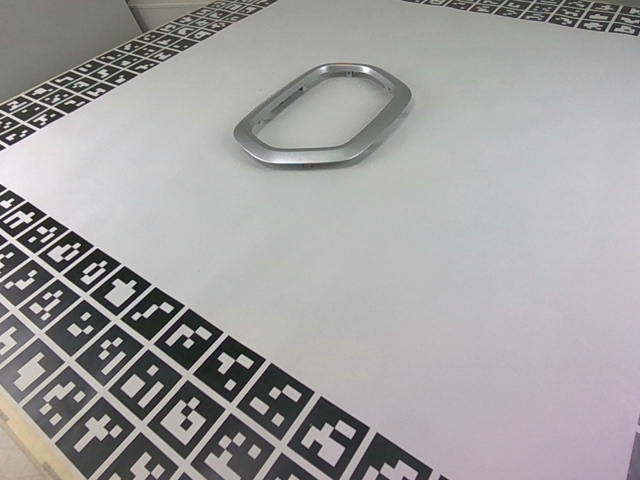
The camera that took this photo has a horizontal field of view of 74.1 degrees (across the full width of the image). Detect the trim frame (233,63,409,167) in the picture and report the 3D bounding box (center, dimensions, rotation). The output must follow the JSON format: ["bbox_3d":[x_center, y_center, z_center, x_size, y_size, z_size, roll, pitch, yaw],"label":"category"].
[{"bbox_3d":[0.003,-0.165,0.537,0.185,0.247,0.027,23,-34,25],"label":"trim frame"}]
